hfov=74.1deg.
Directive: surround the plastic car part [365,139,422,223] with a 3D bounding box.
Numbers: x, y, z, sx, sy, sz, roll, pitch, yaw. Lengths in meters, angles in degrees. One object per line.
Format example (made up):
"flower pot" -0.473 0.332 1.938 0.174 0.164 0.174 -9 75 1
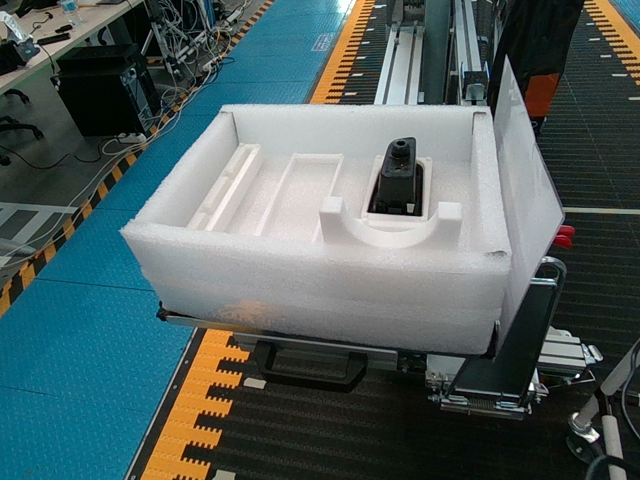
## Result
"plastic car part" 0.097 -0.084 0.527 0.066 0.116 0.071 6 -42 14
